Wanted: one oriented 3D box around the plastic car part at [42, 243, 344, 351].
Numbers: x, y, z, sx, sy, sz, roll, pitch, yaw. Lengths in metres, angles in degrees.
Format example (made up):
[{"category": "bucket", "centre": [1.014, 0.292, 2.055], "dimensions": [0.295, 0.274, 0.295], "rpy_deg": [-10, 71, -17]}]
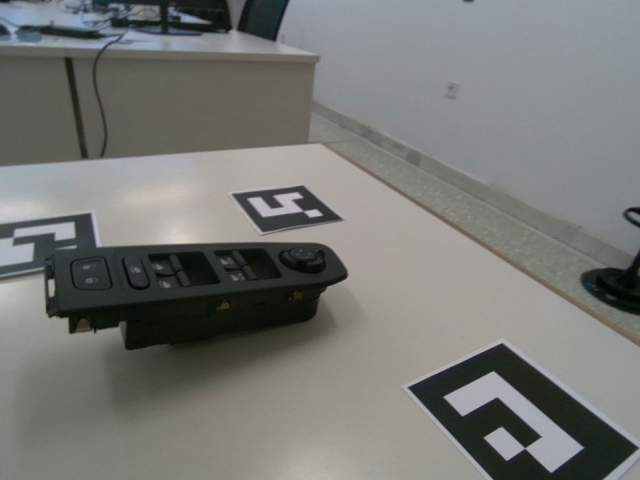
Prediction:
[{"category": "plastic car part", "centre": [-0.072, 0.038, 0.299], "dimensions": [0.201, 0.067, 0.067], "rpy_deg": [-7, 25, -31]}]
